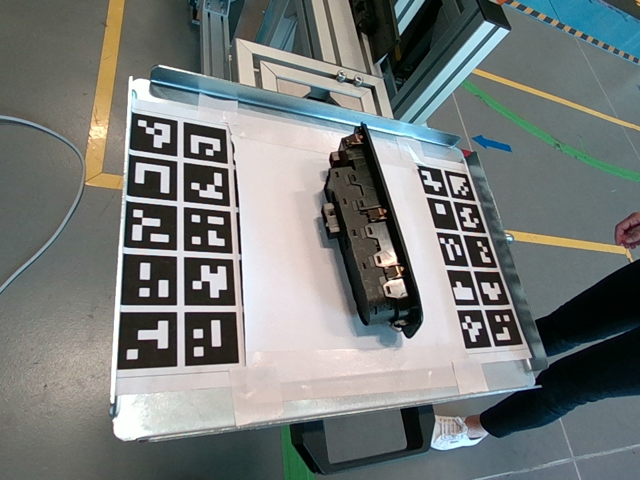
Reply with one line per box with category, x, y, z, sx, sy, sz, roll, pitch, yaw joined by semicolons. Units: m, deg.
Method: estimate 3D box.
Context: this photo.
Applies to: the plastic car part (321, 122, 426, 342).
plastic car part;0.042;-0.006;0.388;0.067;0.203;0.066;-10;-22;-21
